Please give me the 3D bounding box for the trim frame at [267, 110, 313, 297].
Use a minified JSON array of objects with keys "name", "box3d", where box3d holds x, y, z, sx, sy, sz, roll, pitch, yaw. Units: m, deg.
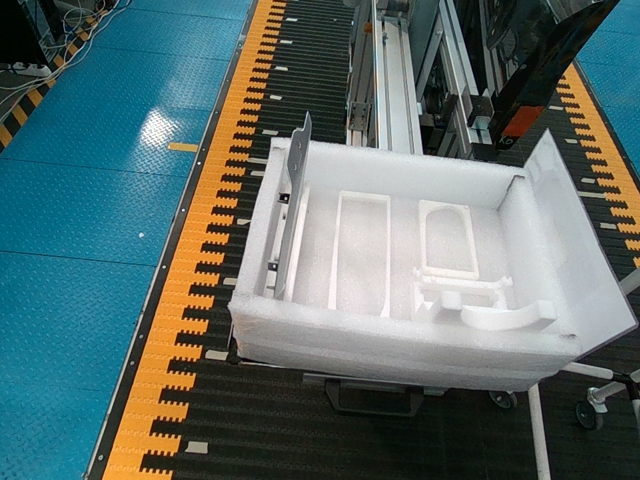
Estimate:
[{"name":"trim frame","box3d":[-0.036,-0.045,0.522,0.027,0.247,0.185,12,-34,-2]}]
